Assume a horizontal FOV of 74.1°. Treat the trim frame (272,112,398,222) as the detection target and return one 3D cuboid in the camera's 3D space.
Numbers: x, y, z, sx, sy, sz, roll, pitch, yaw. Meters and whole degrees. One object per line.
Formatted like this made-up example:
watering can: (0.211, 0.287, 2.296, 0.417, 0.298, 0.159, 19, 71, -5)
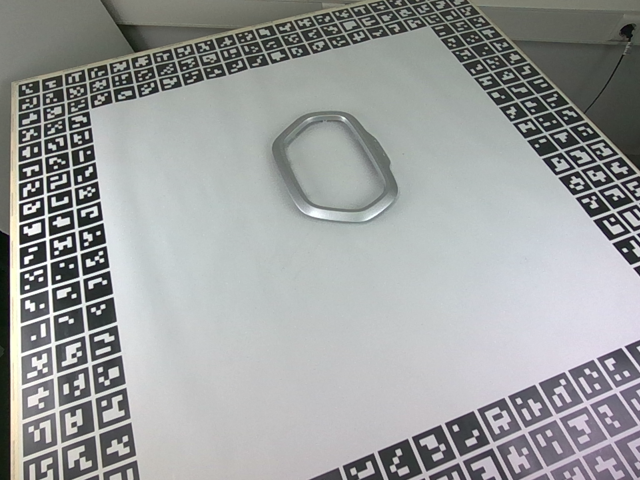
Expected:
trim frame: (0.024, -0.127, 0.708, 0.184, 0.248, 0.027, -22, -30, -9)
